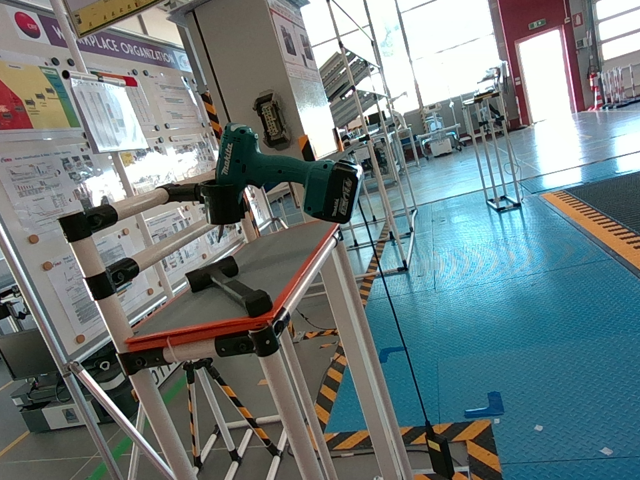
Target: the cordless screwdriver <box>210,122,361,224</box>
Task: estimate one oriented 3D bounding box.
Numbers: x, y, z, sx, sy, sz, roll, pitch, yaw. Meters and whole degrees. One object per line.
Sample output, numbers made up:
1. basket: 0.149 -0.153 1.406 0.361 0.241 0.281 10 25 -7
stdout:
1. cordless screwdriver: -0.066 -0.085 0.702 0.249 0.159 0.074 19 19 9
